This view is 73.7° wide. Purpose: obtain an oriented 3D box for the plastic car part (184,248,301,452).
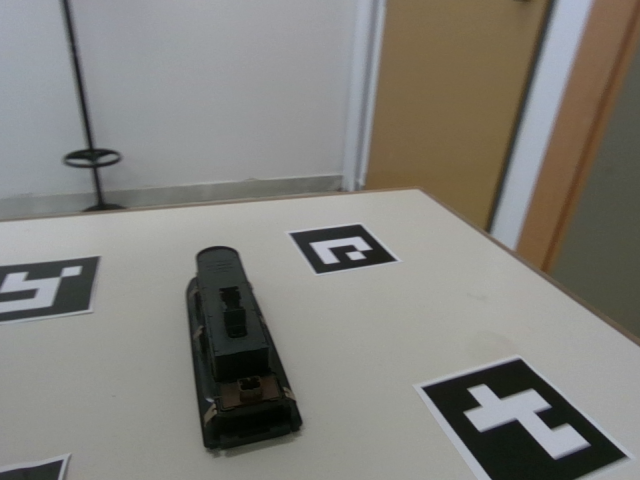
[{"bbox_3d":[-0.078,0.066,0.352,0.066,0.067,0.204,-12,28,-16],"label":"plastic car part"}]
